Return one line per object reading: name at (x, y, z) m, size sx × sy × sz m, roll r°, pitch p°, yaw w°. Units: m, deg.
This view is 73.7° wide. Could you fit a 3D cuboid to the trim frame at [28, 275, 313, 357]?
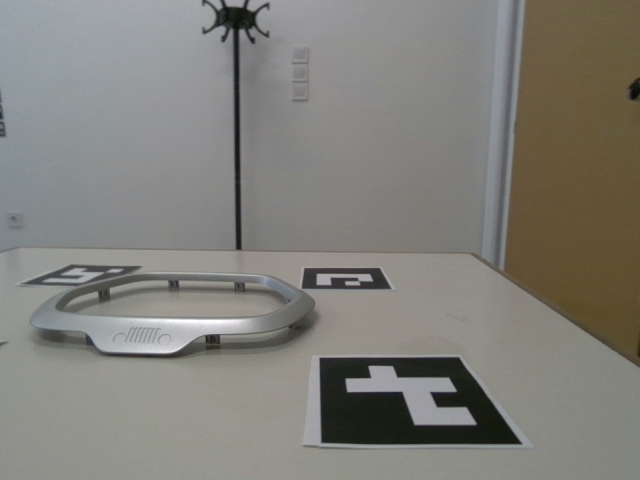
trim frame at (-0.131, 0.062, 0.399) m, size 0.248 × 0.027 × 0.184 m, roll 2°, pitch 8°, yaw 2°
